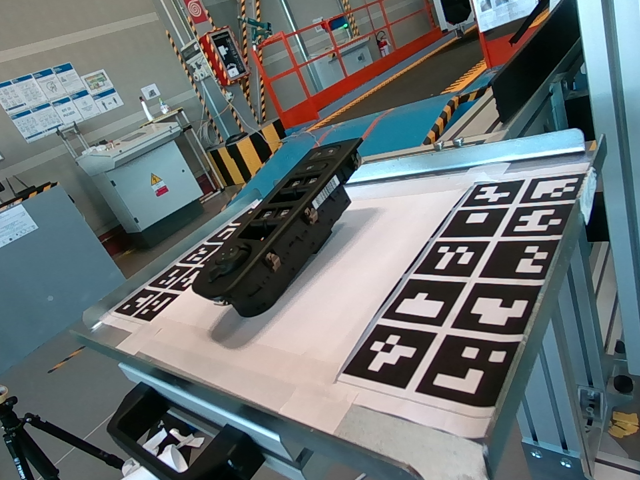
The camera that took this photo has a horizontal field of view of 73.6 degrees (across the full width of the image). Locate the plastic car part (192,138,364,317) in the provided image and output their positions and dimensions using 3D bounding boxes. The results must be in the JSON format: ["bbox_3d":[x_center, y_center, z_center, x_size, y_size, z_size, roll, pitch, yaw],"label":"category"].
[{"bbox_3d":[-0.027,-0.011,0.368,0.067,0.067,0.202,7,42,39],"label":"plastic car part"}]
